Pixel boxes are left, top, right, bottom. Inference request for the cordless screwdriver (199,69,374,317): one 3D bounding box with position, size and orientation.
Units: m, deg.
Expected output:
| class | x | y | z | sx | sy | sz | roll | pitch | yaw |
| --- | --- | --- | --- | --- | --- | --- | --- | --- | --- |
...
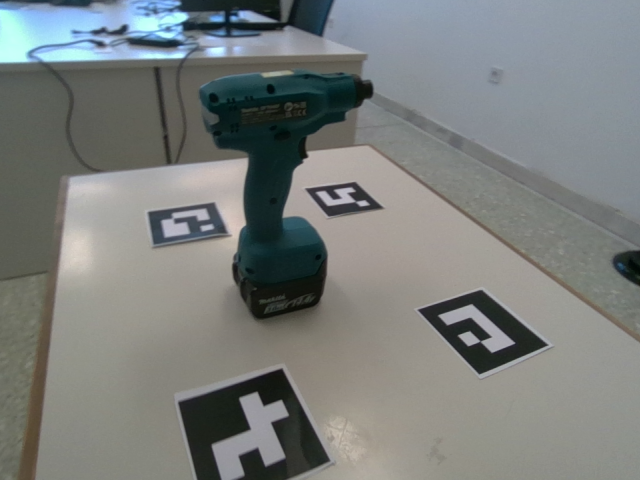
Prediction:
| class | x | y | z | sx | sy | sz | roll | pitch | yaw |
| --- | --- | --- | --- | --- | --- | --- | --- | --- | --- |
| cordless screwdriver | -0.025 | -0.045 | 0.439 | 0.158 | 0.248 | 0.075 | -13 | 37 | -19 |
